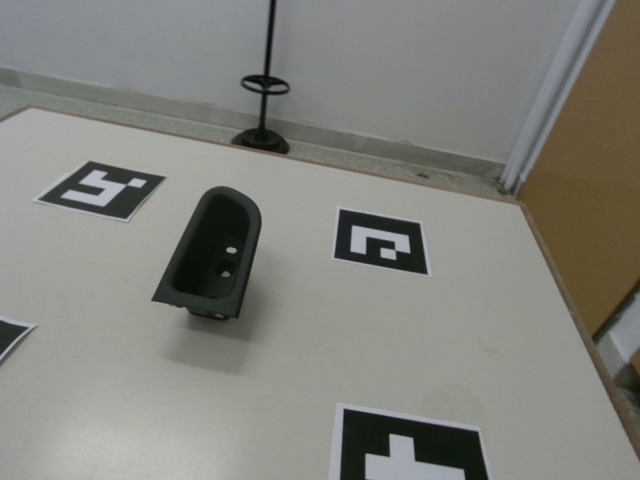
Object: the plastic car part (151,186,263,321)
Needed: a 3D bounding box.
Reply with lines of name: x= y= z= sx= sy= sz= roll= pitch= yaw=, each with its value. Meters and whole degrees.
plastic car part: x=-0.084 y=0.020 z=0.360 sx=0.066 sy=0.116 sz=0.071 roll=12 pitch=-38 yaw=0
